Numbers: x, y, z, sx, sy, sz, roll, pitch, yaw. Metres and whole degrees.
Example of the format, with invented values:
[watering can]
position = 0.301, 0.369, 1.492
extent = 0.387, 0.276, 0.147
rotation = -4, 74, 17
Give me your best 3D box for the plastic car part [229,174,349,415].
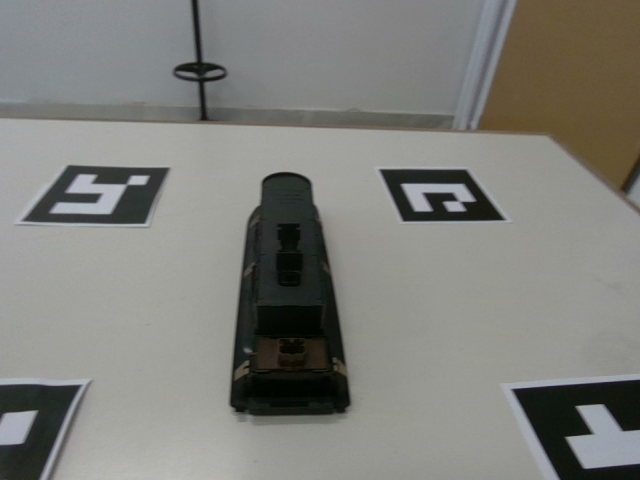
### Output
[plastic car part]
position = -0.026, 0.014, 0.297
extent = 0.066, 0.067, 0.203
rotation = -5, 35, -3
